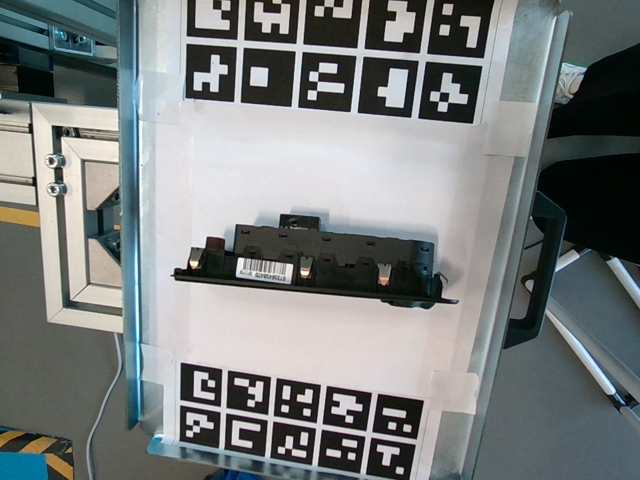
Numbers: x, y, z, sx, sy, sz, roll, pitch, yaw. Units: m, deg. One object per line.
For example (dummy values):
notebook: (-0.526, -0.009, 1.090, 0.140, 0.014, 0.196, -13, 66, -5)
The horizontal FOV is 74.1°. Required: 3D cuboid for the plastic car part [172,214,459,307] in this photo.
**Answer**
plastic car part: (0.000, 0.017, 0.324, 0.203, 0.067, 0.066, 9, -12, 8)
